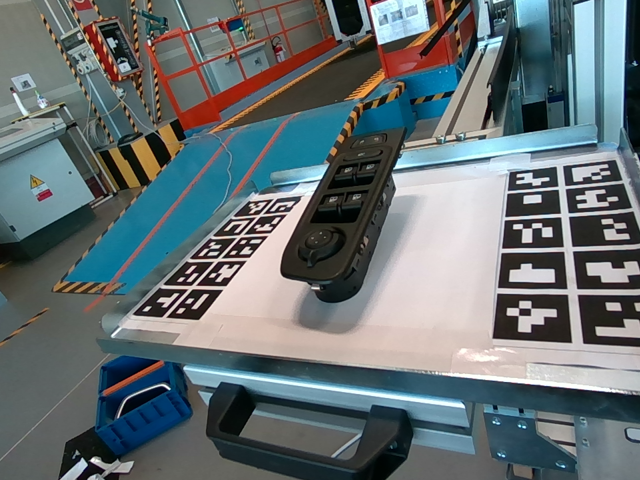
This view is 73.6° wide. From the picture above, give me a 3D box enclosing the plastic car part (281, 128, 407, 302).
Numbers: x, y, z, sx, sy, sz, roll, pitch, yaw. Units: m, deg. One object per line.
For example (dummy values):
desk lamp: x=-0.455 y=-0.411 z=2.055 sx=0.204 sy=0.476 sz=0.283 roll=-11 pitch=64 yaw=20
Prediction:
plastic car part: x=0.026 y=-0.023 z=0.366 sx=0.067 sy=0.067 sz=0.202 roll=3 pitch=39 yaw=24
